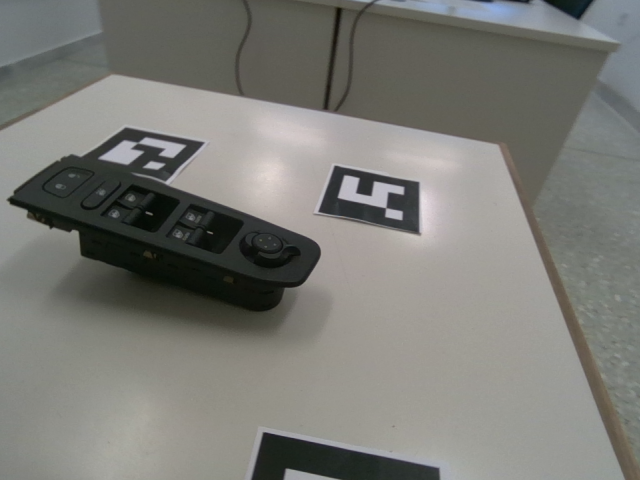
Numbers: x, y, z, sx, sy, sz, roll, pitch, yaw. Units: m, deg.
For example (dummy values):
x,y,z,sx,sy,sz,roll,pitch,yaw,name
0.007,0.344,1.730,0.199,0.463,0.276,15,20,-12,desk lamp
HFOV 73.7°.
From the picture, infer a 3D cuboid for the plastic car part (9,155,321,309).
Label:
x,y,z,sx,sy,sz,roll,pitch,yaw,name
-0.103,0.003,0.305,0.203,0.067,0.066,14,32,4,plastic car part
